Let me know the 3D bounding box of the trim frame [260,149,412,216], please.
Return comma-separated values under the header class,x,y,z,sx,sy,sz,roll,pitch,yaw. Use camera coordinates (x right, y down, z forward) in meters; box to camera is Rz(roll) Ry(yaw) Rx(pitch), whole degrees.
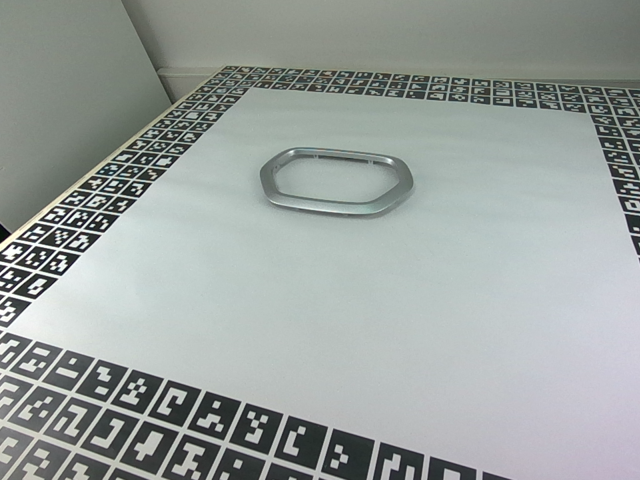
class,x,y,z,sx,sy,sz,roll,pitch,yaw
trim frame,0.022,-0.100,0.681,0.249,0.027,0.183,6,44,14
